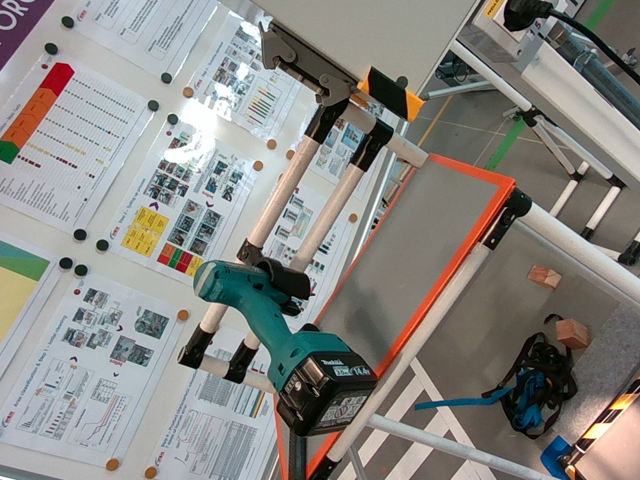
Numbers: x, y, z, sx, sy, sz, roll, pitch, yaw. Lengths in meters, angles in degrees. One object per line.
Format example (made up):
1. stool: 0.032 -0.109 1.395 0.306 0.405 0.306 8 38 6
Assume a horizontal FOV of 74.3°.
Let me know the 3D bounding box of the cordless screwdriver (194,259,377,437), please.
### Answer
1. cordless screwdriver: -0.035 0.113 0.518 0.159 0.074 0.248 16 19 -50
